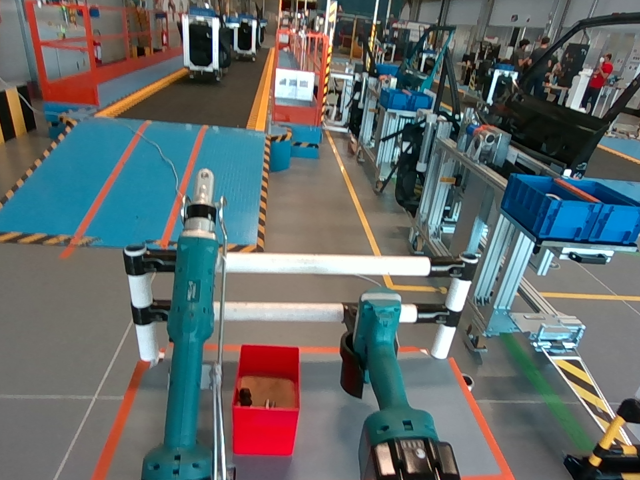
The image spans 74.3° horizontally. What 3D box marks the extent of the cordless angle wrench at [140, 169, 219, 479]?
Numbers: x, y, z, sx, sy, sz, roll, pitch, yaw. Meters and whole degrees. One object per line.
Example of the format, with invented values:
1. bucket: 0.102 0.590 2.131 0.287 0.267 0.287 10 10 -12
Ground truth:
1. cordless angle wrench: -0.158 0.102 0.518 0.074 0.422 0.098 4 -21 -14

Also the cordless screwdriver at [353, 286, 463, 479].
1. cordless screwdriver: 0.073 0.188 0.467 0.074 0.159 0.248 1 34 -4
